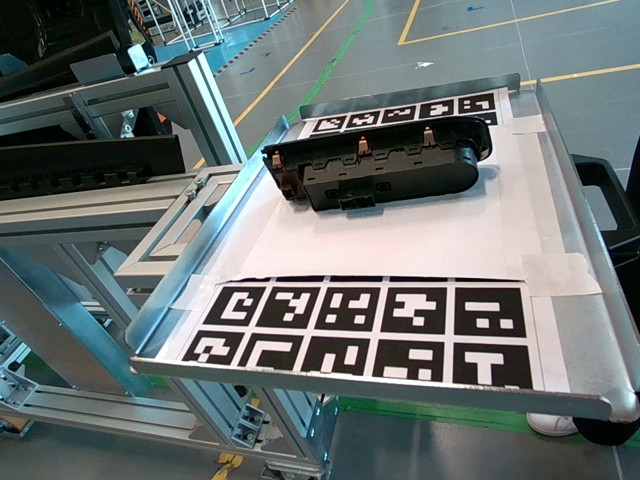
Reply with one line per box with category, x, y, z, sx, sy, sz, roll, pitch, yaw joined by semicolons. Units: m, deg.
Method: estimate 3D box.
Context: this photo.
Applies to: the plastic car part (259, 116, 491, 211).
plastic car part;0.049;-0.063;0.377;0.203;0.067;0.066;-9;-41;10
